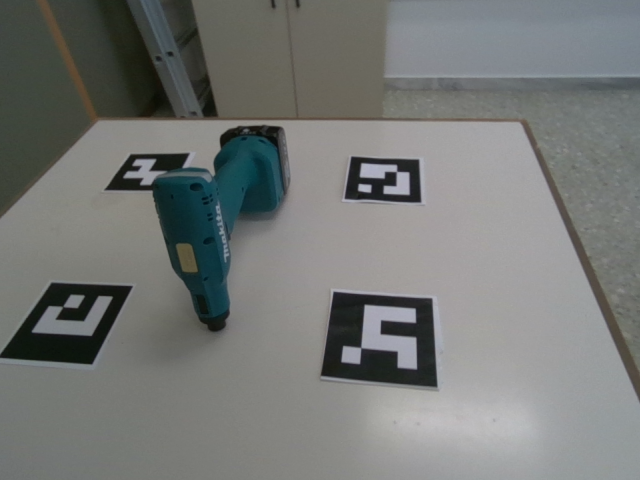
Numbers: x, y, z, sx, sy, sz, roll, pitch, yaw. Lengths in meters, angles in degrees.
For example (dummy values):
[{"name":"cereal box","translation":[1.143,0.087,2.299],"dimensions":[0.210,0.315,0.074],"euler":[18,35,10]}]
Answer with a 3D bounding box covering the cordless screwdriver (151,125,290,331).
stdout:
[{"name":"cordless screwdriver","translation":[-0.093,-0.031,0.473],"dimensions":[0.074,0.159,0.248],"euler":[0,28,10]}]
